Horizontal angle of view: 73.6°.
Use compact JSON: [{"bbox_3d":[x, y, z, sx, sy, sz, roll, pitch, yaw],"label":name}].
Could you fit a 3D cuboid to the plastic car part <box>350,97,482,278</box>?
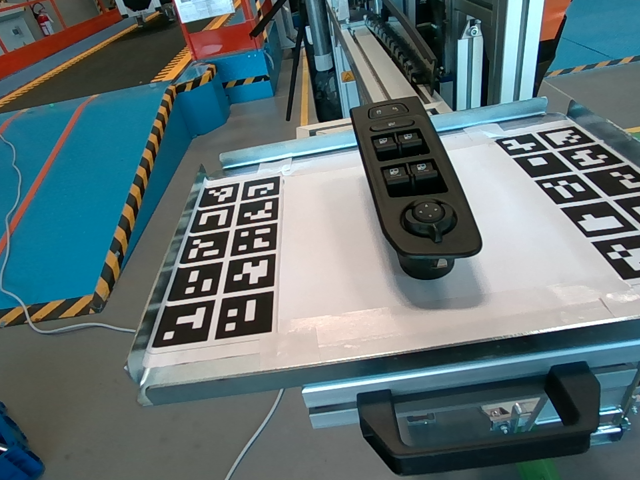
[{"bbox_3d":[0.068,-0.045,0.348,0.066,0.067,0.202,-4,41,-2],"label":"plastic car part"}]
